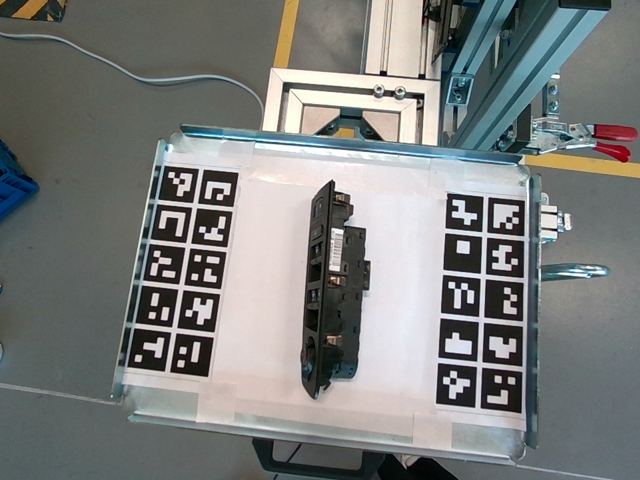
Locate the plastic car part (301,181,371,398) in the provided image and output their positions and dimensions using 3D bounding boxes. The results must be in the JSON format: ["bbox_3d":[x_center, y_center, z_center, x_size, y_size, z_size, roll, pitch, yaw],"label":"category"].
[{"bbox_3d":[0.014,0.050,0.423,0.067,0.203,0.067,13,-13,-24],"label":"plastic car part"}]
